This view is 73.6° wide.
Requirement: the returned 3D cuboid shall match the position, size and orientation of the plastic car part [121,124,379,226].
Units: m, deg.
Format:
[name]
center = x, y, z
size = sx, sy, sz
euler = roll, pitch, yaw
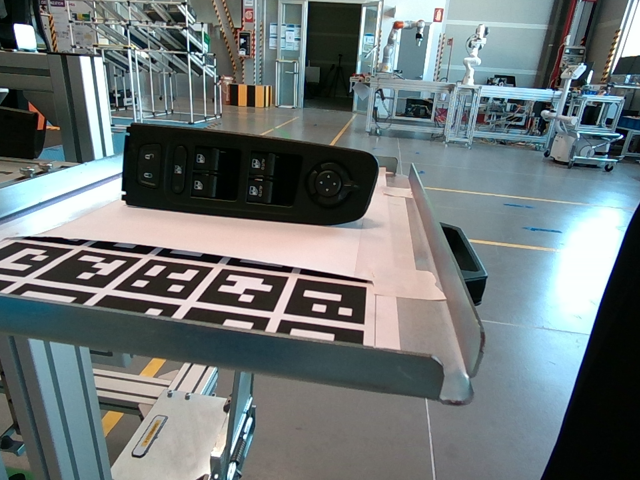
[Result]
[plastic car part]
center = -0.055, -0.048, 0.355
size = 0.204, 0.066, 0.067
euler = 6, -5, 8
